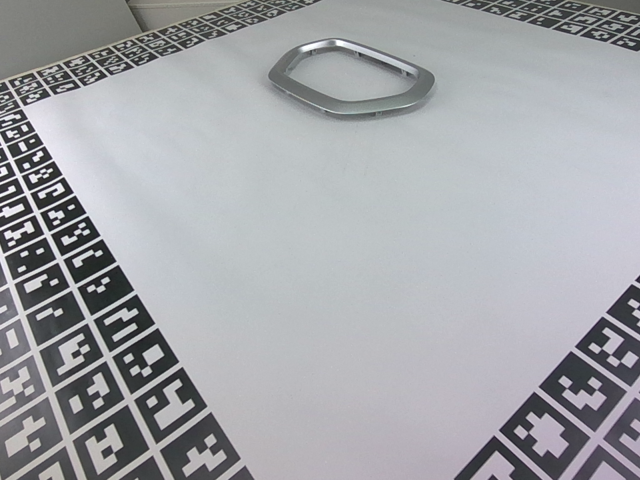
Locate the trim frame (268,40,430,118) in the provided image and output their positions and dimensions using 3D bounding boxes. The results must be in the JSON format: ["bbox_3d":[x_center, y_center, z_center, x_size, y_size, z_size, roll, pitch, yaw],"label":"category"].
[{"bbox_3d":[0.037,-0.236,0.609,0.183,0.027,0.249,-35,51,-23],"label":"trim frame"}]
